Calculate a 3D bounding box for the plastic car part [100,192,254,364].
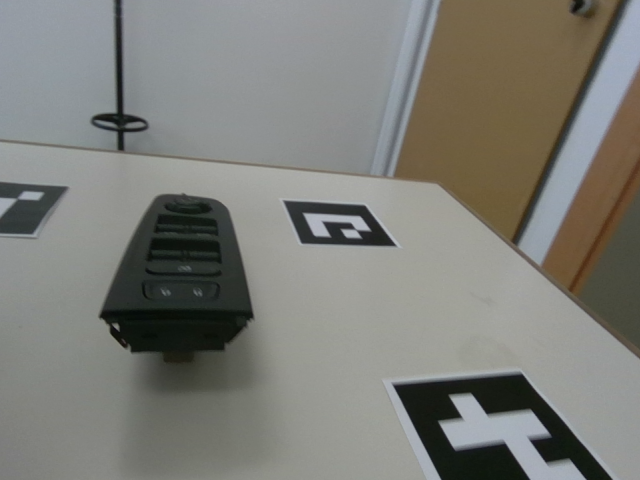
[{"bbox_3d":[-0.087,0.017,0.285,0.066,0.067,0.204,-3,27,-14],"label":"plastic car part"}]
